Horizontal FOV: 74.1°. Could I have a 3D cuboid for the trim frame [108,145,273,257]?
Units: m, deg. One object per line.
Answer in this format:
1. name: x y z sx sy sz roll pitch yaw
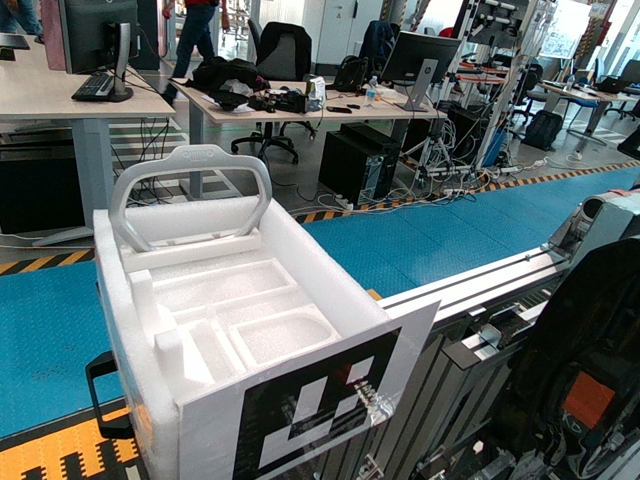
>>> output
1. trim frame: -0.184 -0.055 0.640 0.247 0.185 0.027 -11 44 -28
